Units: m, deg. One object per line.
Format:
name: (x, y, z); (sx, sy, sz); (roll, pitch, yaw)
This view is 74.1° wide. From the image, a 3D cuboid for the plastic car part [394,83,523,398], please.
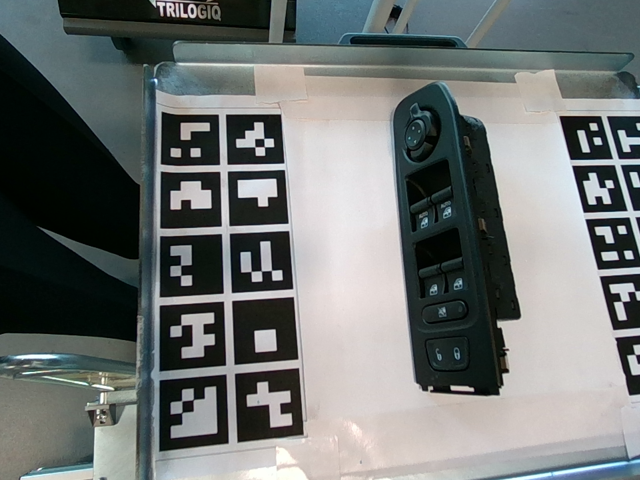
plastic car part: (0.091, -0.008, 0.277); (0.067, 0.202, 0.066); (-4, -15, -15)
